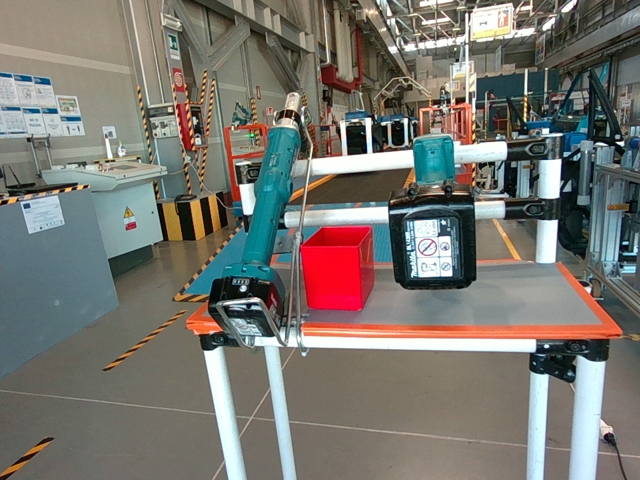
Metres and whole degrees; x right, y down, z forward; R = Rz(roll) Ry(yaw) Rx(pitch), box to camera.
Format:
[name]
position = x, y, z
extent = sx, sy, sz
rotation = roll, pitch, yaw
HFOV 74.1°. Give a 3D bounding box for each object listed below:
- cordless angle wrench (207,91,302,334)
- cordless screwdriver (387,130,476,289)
[cordless angle wrench]
position = -0.069, -0.075, 0.630
extent = 0.074, 0.421, 0.098
rotation = 0, -32, 12
[cordless screwdriver]
position = 0.132, -0.022, 0.484
extent = 0.074, 0.159, 0.248
rotation = -3, 24, 17
